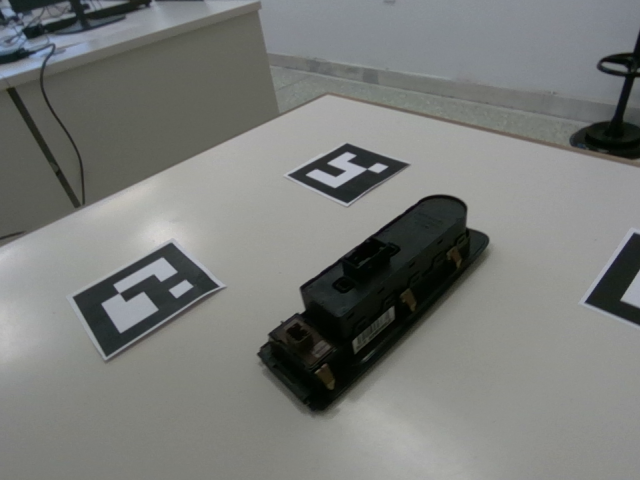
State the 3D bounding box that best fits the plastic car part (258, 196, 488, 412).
[{"bbox_3d":[0.046,0.024,0.311,0.201,0.067,0.067,-31,34,-29],"label":"plastic car part"}]
